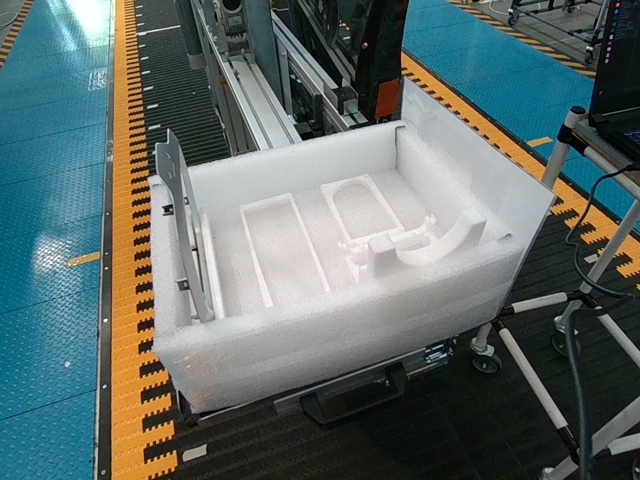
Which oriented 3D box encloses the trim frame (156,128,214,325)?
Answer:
[{"bbox_3d":[-0.150,-0.017,0.475,0.027,0.248,0.184,-10,-42,-11],"label":"trim frame"}]
